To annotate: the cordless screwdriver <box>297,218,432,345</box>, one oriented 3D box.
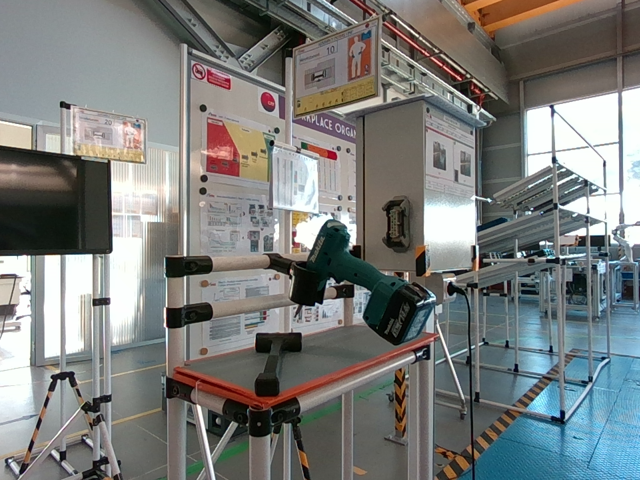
[{"bbox_3d":[0.059,0.088,0.743,0.074,0.159,0.249,-3,33,-48],"label":"cordless screwdriver"}]
